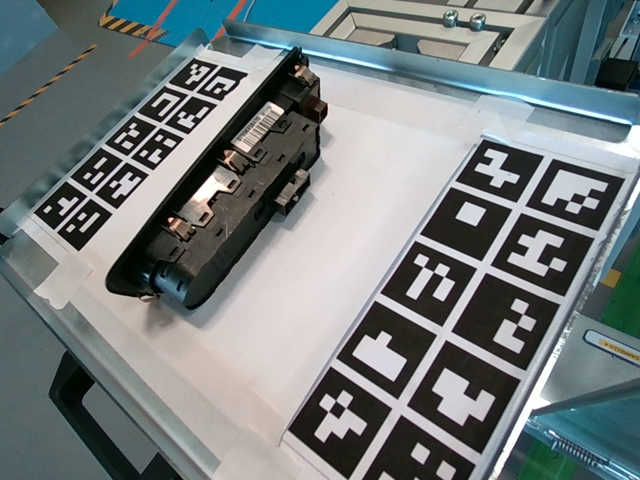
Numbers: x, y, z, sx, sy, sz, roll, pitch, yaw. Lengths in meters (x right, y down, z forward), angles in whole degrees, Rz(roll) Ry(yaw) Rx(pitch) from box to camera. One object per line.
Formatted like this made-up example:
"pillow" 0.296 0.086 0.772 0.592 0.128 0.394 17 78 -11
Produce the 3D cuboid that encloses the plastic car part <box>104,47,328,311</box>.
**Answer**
"plastic car part" -0.053 -0.032 0.290 0.067 0.202 0.066 38 -17 6
